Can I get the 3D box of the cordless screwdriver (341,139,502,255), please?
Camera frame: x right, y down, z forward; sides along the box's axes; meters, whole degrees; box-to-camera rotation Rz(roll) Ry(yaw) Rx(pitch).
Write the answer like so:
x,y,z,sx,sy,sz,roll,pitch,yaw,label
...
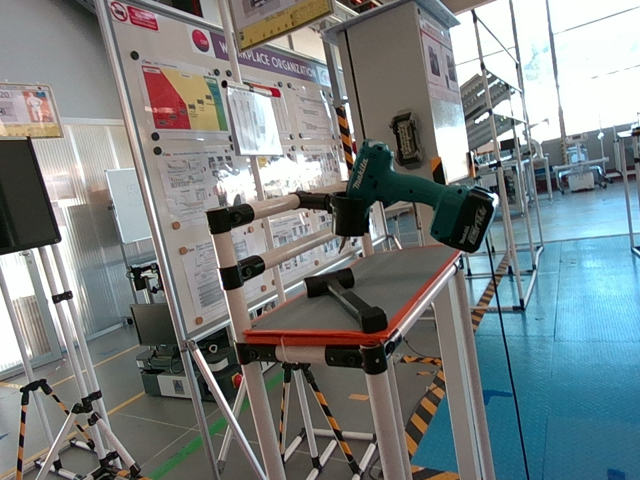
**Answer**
x,y,z,sx,sy,sz,roll,pitch,yaw,label
0.151,-0.049,0.691,0.249,0.159,0.074,28,24,23,cordless screwdriver
